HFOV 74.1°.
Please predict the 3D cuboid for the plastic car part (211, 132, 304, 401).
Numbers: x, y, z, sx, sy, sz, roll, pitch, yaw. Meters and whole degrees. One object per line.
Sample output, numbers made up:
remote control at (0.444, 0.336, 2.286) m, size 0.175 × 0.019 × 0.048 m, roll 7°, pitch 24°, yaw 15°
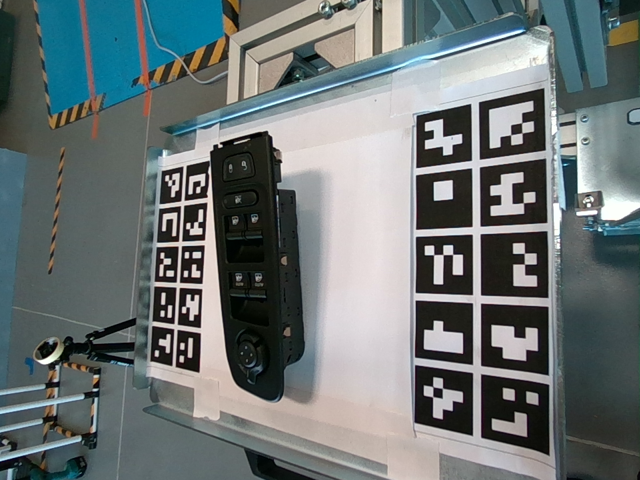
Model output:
plastic car part at (-0.047, 0.023, 0.347) m, size 0.067 × 0.202 × 0.067 m, roll -3°, pitch -3°, yaw 28°
